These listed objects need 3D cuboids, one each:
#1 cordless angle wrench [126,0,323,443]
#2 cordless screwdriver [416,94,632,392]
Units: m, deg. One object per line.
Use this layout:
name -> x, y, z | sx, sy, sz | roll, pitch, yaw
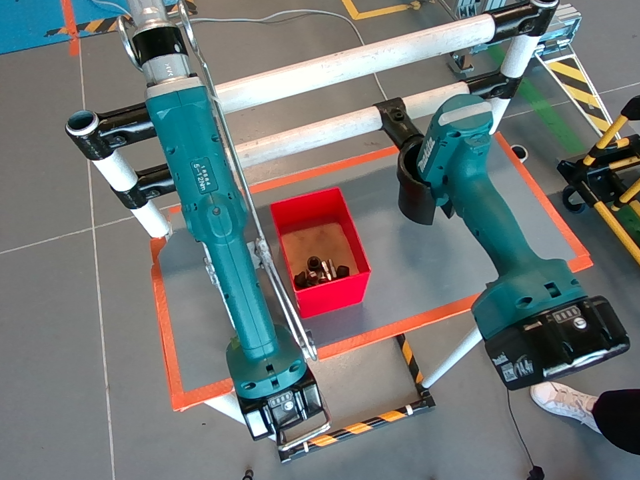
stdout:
cordless angle wrench -> -0.094, -0.024, 0.381 | 0.074, 0.423, 0.098 | -19, 14, -15
cordless screwdriver -> 0.156, 0.007, 0.398 | 0.074, 0.248, 0.159 | -17, -20, -6
